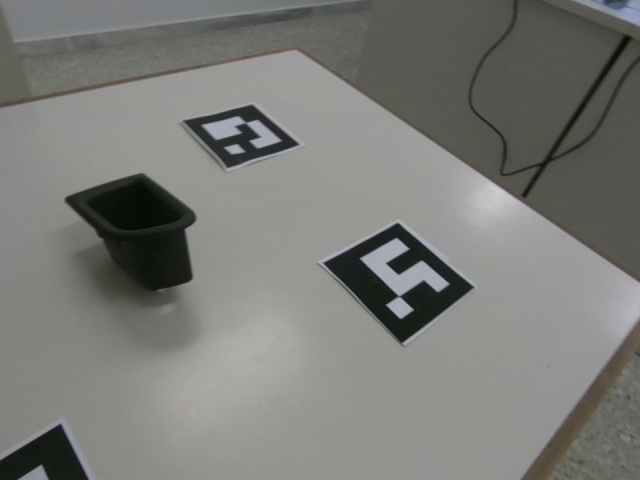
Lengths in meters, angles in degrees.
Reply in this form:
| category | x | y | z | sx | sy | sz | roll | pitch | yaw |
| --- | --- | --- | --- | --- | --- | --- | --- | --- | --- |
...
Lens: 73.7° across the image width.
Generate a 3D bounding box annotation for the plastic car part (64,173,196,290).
| category | x | y | z | sx | sy | sz | roll | pitch | yaw |
| --- | --- | --- | --- | --- | --- | --- | --- | --- | --- |
| plastic car part | -0.133 | 0.001 | 0.321 | 0.065 | 0.071 | 0.117 | -28 | 40 | -31 |
